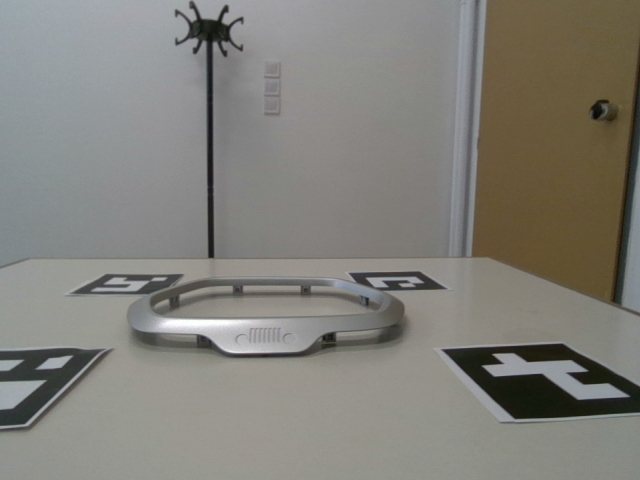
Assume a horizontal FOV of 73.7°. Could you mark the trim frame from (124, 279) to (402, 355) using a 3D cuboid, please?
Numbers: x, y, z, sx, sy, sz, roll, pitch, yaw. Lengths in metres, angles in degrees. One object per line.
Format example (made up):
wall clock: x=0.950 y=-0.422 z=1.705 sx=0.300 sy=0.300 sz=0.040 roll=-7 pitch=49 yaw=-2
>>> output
trim frame: x=-0.049 y=0.063 z=0.393 sx=0.248 sy=0.027 sz=0.184 roll=2 pitch=6 yaw=-6
